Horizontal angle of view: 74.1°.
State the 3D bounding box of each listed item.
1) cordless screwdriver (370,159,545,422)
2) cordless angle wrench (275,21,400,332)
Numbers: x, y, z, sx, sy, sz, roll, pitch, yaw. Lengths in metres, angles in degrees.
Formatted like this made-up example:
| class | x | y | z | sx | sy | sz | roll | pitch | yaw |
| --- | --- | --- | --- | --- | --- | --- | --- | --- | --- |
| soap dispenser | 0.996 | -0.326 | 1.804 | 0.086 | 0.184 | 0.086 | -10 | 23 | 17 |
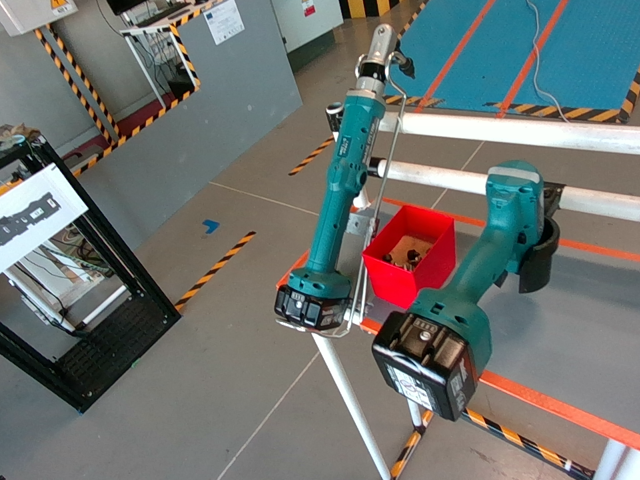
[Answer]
| class | x | y | z | sx | sy | sz | roll | pitch | yaw |
| --- | --- | --- | --- | --- | --- | --- | --- | --- | --- |
| cordless screwdriver | 0.159 | 0.056 | 0.427 | 0.074 | 0.248 | 0.159 | 19 | -29 | 40 |
| cordless angle wrench | 0.040 | -0.088 | 0.584 | 0.074 | 0.422 | 0.098 | 17 | 4 | 37 |
